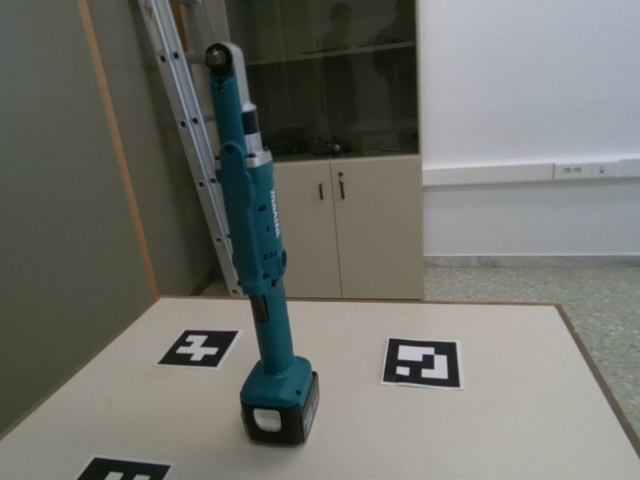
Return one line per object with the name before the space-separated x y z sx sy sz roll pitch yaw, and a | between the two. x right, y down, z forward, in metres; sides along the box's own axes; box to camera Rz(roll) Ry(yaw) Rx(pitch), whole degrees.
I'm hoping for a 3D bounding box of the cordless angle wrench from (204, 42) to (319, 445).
cordless angle wrench | -0.065 0.023 0.451 0.075 0.422 0.097 -1 21 14
